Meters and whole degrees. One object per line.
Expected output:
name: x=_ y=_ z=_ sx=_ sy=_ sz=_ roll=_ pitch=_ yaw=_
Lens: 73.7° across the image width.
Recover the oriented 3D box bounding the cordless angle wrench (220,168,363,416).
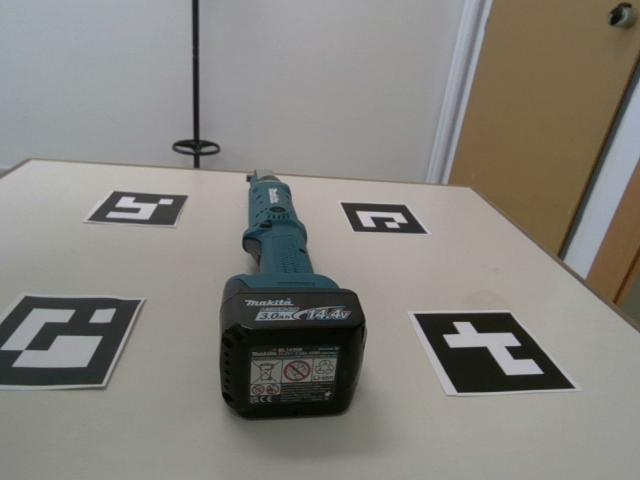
cordless angle wrench: x=-0.049 y=-0.006 z=0.460 sx=0.097 sy=0.074 sz=0.424 roll=0 pitch=26 yaw=-10
